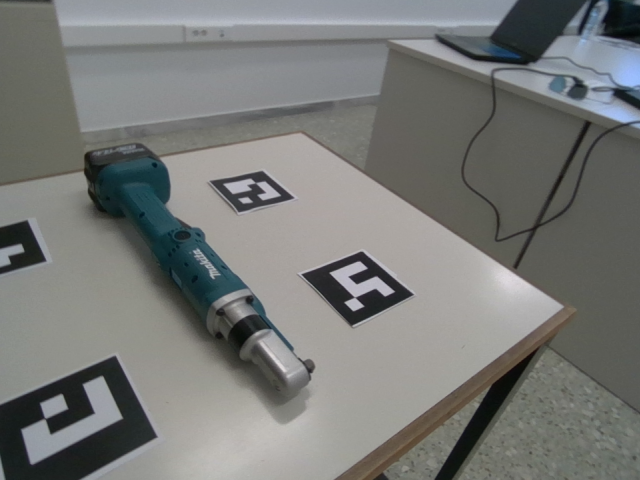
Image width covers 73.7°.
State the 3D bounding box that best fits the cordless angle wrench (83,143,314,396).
[{"bbox_3d":[-0.156,0.014,0.489,0.097,0.074,0.426,-21,47,-35],"label":"cordless angle wrench"}]
